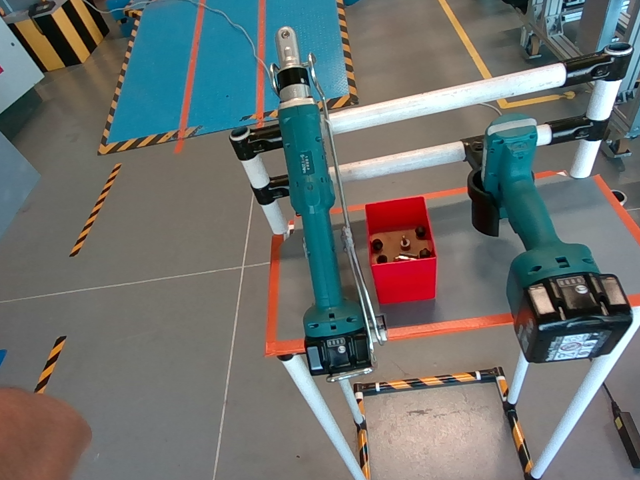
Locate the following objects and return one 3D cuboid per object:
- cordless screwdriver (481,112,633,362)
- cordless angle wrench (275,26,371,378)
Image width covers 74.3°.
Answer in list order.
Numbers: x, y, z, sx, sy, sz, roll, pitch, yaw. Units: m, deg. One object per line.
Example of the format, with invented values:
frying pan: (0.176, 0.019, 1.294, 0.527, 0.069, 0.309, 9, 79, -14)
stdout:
cordless screwdriver: (0.224, 0.003, 0.453, 0.074, 0.248, 0.159, -9, -34, 11)
cordless angle wrench: (-0.010, -0.054, 0.519, 0.074, 0.422, 0.098, -9, -2, 1)
